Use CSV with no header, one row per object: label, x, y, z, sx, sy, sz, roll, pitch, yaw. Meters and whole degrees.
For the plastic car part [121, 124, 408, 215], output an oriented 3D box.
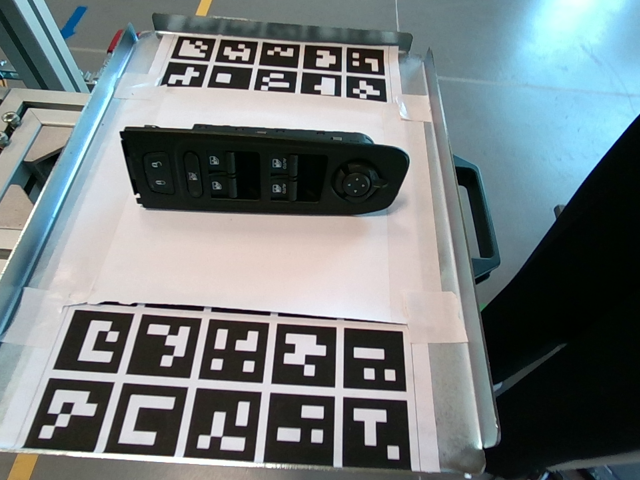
plastic car part,-0.037,-0.057,0.331,0.203,0.067,0.067,5,31,1
